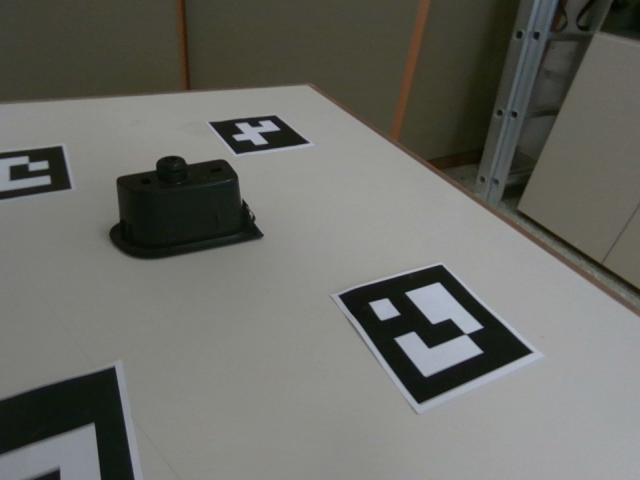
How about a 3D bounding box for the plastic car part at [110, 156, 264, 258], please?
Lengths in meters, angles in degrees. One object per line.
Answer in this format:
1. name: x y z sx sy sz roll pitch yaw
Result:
1. plastic car part: -0.111 -0.033 0.348 0.115 0.071 0.066 -11 38 -26
